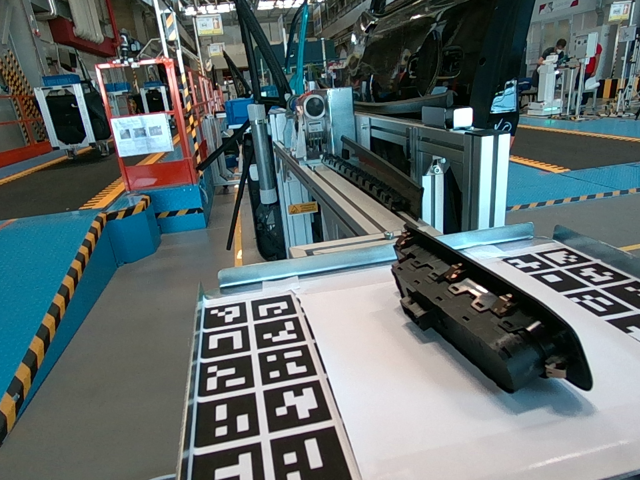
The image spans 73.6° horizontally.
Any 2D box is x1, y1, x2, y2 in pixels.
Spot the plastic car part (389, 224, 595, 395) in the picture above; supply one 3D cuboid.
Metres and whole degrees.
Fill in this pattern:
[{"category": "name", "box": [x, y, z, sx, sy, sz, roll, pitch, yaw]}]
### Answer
[{"category": "plastic car part", "box": [0.103, 0.047, 0.325, 0.067, 0.066, 0.203, -23, 23, -14]}]
